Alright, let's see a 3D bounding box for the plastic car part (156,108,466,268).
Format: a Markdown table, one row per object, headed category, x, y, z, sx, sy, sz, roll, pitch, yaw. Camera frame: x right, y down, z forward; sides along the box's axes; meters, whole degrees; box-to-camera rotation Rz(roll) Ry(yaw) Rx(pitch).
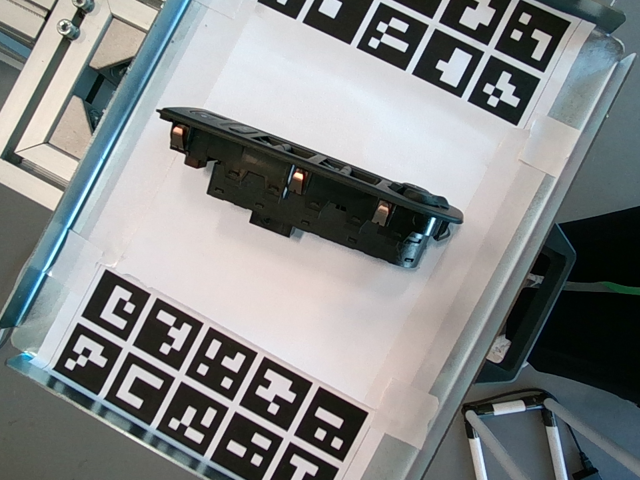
| category | x | y | z | sx | sy | sz | roll | pitch | yaw |
| --- | --- | --- | --- | --- | --- | --- | --- | --- | --- |
| plastic car part | -0.007 | -0.032 | 0.281 | 0.203 | 0.067 | 0.066 | 17 | 9 | 7 |
